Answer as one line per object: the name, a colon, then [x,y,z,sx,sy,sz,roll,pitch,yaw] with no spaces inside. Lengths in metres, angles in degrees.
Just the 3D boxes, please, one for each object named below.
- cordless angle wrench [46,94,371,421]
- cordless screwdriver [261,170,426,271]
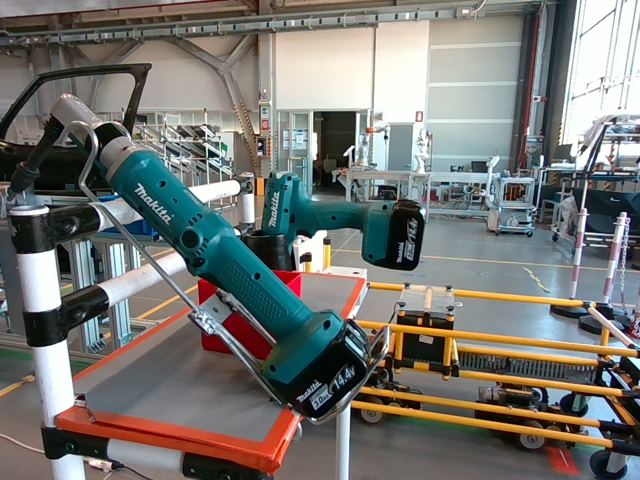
cordless angle wrench: [-0.124,0.000,0.439,0.423,0.098,0.074,44,11,2]
cordless screwdriver: [0.028,-0.006,0.640,0.249,0.159,0.074,13,17,13]
